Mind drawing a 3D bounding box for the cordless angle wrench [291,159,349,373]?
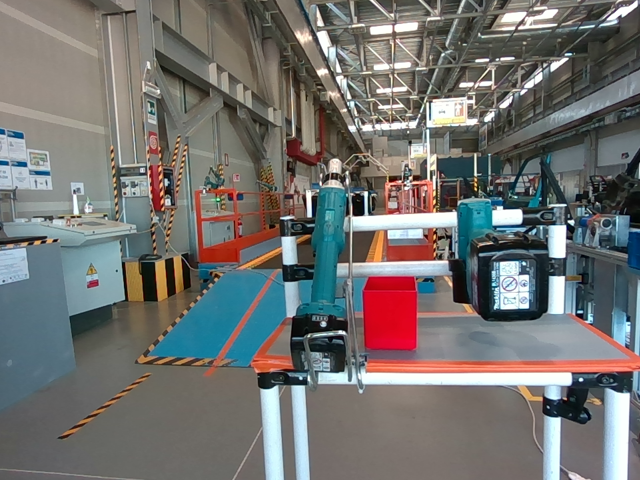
[{"bbox_3d":[0.015,0.003,0.696,0.074,0.421,0.098,3,-41,4],"label":"cordless angle wrench"}]

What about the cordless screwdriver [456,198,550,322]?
[{"bbox_3d":[0.227,0.040,0.570,0.074,0.159,0.248,-3,15,10],"label":"cordless screwdriver"}]
